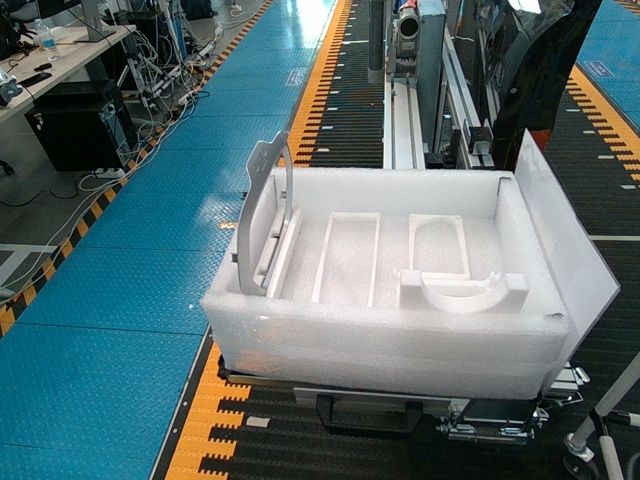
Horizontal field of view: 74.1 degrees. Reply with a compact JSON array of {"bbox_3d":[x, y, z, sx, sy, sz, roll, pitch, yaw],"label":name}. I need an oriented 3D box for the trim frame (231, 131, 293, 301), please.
[{"bbox_3d":[-0.069,-0.035,0.559,0.027,0.184,0.247,8,46,9],"label":"trim frame"}]
